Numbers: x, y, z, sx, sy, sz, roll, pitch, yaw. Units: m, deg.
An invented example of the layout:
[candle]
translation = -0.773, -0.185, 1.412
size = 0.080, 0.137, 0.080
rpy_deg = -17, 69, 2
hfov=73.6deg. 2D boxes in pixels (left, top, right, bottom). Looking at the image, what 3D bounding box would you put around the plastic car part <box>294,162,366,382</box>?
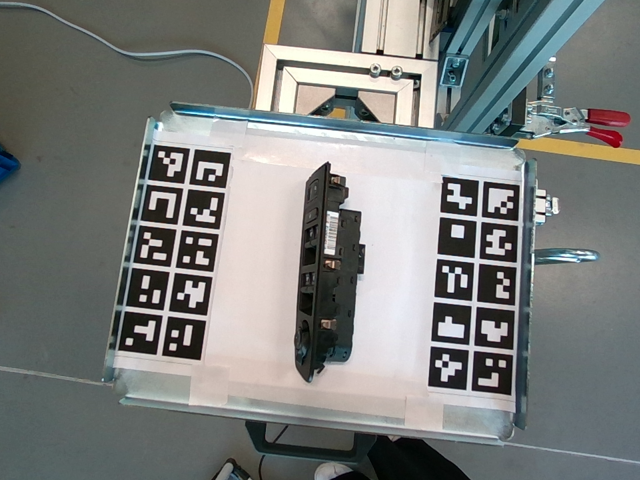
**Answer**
[plastic car part]
translation = 0.009, 0.034, 0.420
size = 0.067, 0.203, 0.067
rpy_deg = 13, -11, -26
